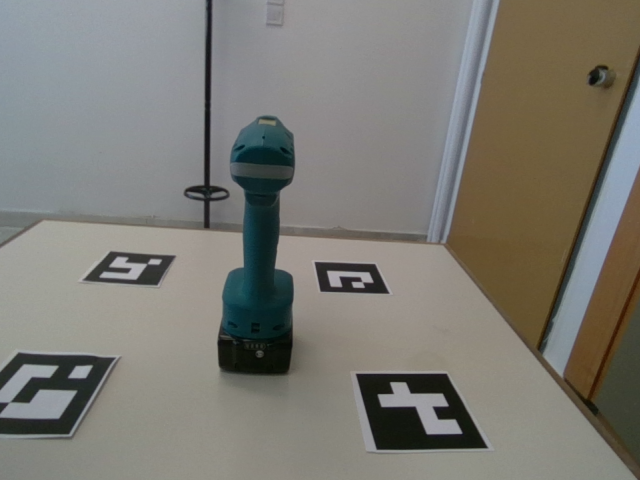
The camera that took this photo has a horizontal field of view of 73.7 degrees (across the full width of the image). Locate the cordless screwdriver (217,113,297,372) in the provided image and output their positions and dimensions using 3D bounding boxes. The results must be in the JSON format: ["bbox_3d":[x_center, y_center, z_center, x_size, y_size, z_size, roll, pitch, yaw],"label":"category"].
[{"bbox_3d":[-0.057,0.001,0.435,0.074,0.249,0.159,4,27,-5],"label":"cordless screwdriver"}]
